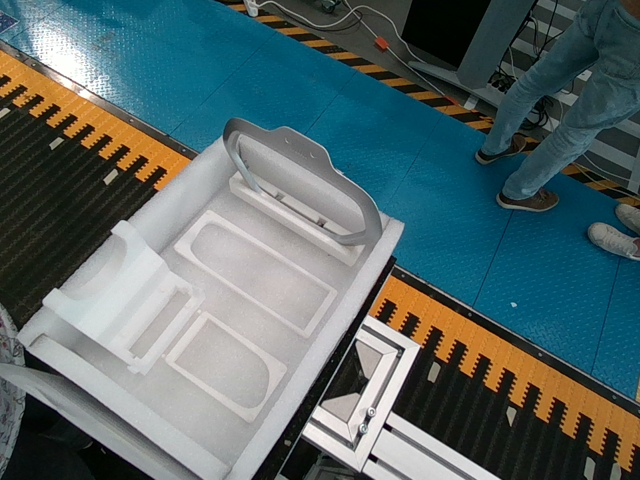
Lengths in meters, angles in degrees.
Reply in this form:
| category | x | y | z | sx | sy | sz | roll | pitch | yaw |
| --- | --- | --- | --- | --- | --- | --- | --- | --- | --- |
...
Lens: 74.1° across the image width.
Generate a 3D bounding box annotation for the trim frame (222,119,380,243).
| category | x | y | z | sx | sy | sz | roll | pitch | yaw |
| --- | --- | --- | --- | --- | --- | --- | --- | --- | --- |
| trim frame | -0.028 | -0.073 | 0.565 | 0.249 | 0.027 | 0.184 | 32 | -23 | 11 |
